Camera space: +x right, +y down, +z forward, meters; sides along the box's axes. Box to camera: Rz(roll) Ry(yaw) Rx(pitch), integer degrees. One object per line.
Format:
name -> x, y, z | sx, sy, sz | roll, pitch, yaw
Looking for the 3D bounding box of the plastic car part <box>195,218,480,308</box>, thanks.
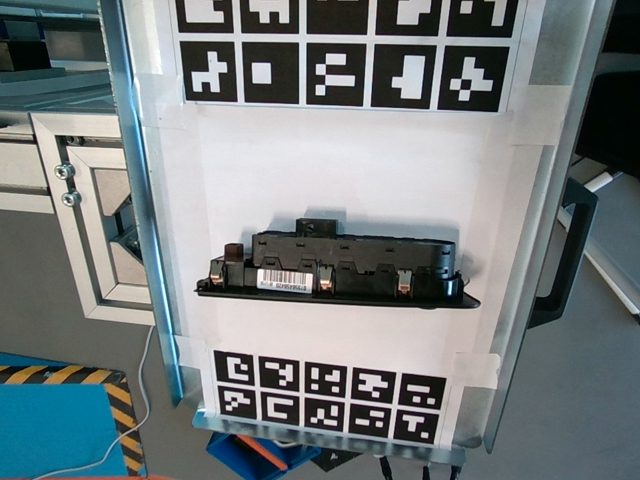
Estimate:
plastic car part -> 0.014, 0.018, 0.323 | 0.203, 0.067, 0.066 | 7, -1, 9
